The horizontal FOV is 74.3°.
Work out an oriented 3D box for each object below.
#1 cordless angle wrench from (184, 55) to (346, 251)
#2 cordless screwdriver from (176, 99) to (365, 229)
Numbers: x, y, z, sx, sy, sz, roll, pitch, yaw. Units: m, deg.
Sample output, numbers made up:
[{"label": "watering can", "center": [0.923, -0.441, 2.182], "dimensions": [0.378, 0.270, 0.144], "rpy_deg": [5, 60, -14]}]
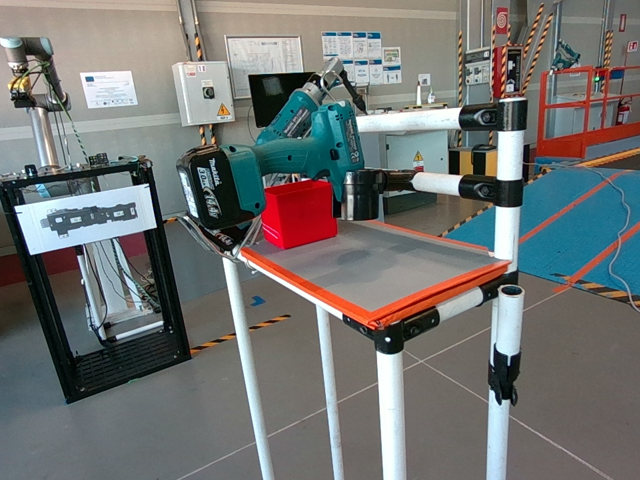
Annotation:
[{"label": "cordless angle wrench", "center": [-0.083, -0.176, 0.778], "dimensions": [0.074, 0.422, 0.098], "rpy_deg": [26, -13, 50]}, {"label": "cordless screwdriver", "center": [-0.047, -0.077, 0.556], "dimensions": [0.248, 0.159, 0.074], "rpy_deg": [-23, 21, -24]}]
